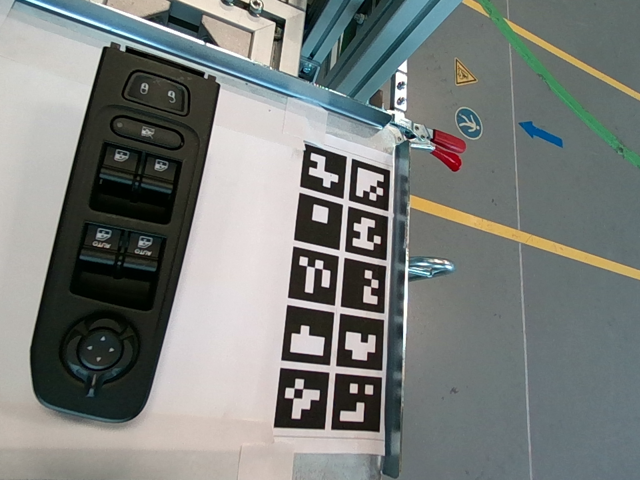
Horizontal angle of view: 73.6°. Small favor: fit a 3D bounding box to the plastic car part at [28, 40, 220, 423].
[{"bbox_3d":[-0.115,-0.004,0.248,0.066,0.202,0.067,14,-15,-30],"label":"plastic car part"}]
